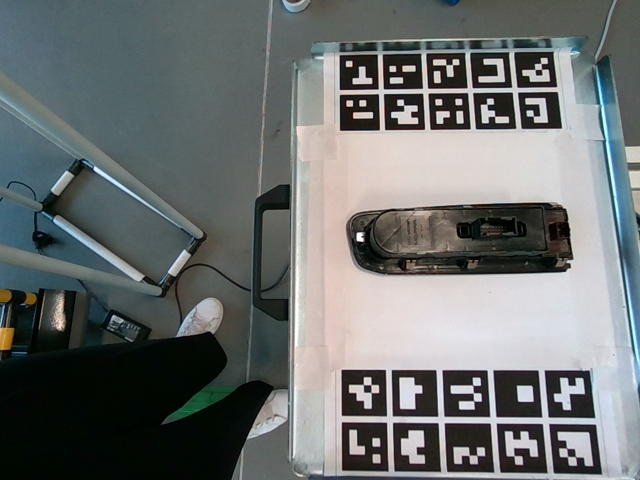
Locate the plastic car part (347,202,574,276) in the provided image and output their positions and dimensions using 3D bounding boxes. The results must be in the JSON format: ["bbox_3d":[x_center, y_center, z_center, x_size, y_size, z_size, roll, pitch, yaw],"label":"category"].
[{"bbox_3d":[0.126,-0.002,0.375,0.203,0.066,0.067,-2,-5,3],"label":"plastic car part"}]
